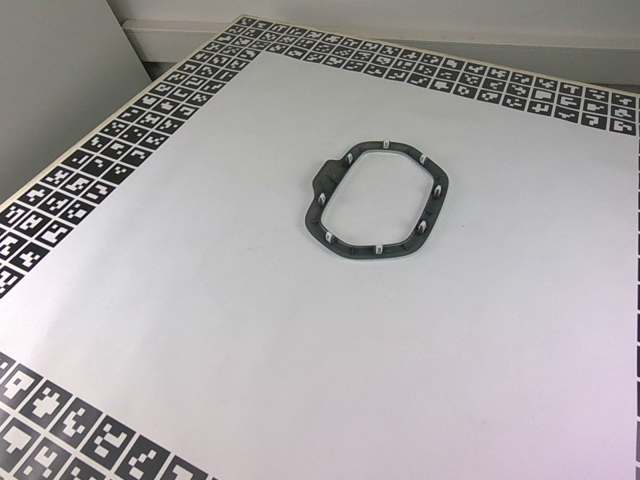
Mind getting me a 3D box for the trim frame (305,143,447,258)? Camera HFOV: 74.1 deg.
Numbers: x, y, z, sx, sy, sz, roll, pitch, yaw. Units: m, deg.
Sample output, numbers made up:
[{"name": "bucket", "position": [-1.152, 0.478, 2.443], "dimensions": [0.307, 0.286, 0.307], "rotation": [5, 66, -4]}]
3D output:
[{"name": "trim frame", "position": [0.083, -0.067, 0.618], "dimensions": [0.185, 0.247, 0.027], "rotation": [20, -35, 19]}]
